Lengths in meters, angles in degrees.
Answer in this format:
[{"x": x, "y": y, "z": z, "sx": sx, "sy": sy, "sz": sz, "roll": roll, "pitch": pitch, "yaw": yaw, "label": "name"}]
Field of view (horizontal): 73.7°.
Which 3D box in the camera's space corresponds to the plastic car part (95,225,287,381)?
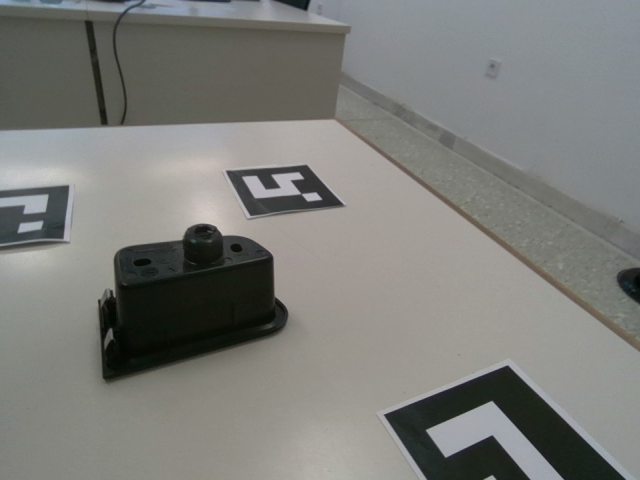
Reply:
[{"x": -0.079, "y": 0.027, "z": 0.264, "sx": 0.115, "sy": 0.071, "sz": 0.066, "roll": -12, "pitch": 36, "yaw": -24, "label": "plastic car part"}]
